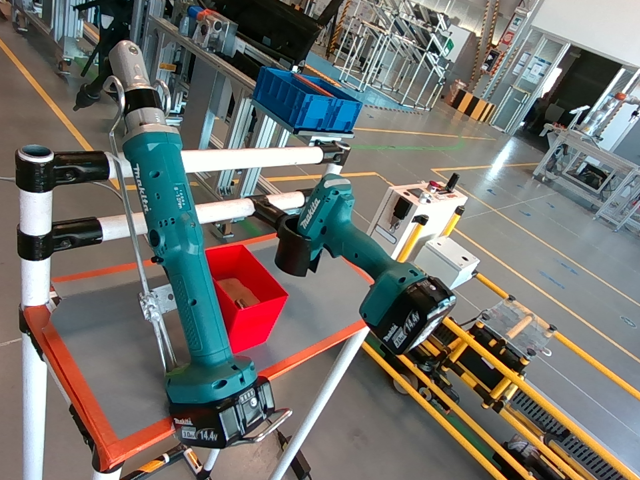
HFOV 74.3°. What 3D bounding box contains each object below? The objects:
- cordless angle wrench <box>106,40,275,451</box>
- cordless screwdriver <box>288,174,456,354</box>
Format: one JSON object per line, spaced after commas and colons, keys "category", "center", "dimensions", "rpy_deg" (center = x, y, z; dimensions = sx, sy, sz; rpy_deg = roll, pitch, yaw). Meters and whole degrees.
{"category": "cordless angle wrench", "center": [-0.152, -0.003, 0.443], "dimensions": [0.098, 0.423, 0.074], "rpy_deg": [-15, 0, 35]}
{"category": "cordless screwdriver", "center": [0.051, 0.044, 0.587], "dimensions": [0.074, 0.160, 0.248], "rpy_deg": [-15, 56, -46]}
